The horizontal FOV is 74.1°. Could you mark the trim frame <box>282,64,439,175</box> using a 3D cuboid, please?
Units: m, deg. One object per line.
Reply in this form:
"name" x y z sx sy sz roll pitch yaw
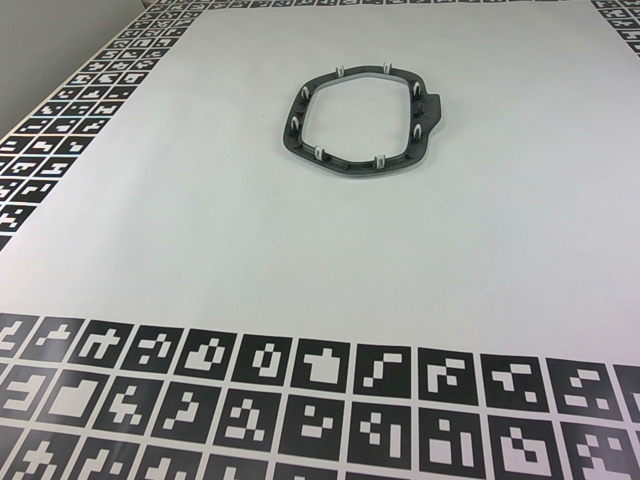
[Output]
"trim frame" 0.051 -0.160 0.528 0.185 0.247 0.027 4 -44 9
